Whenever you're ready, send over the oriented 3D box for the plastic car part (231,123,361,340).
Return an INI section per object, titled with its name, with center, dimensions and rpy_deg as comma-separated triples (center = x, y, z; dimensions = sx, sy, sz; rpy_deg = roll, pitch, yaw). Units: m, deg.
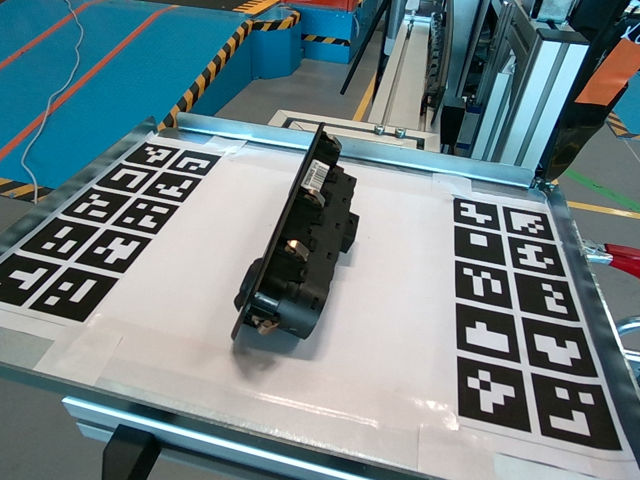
[plastic car part]
center = -0.009, -0.005, 0.309
dimensions = 0.067, 0.067, 0.202
rpy_deg = 33, 39, -8
